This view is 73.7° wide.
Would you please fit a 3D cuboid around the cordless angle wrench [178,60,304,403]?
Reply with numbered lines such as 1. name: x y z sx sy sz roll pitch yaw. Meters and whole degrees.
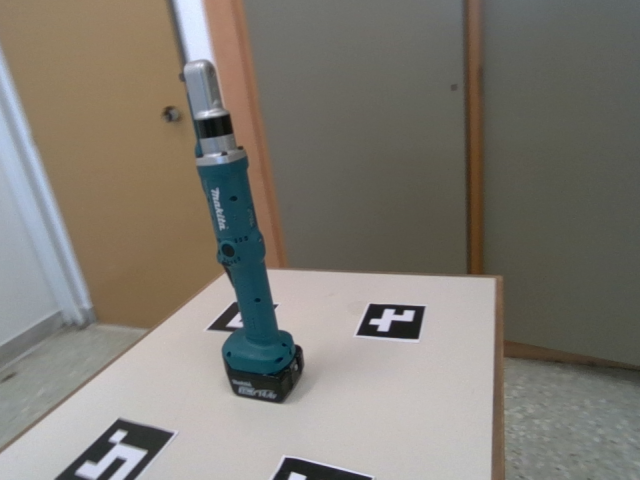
1. cordless angle wrench: -0.101 0.004 0.529 0.099 0.422 0.074 0 21 23
